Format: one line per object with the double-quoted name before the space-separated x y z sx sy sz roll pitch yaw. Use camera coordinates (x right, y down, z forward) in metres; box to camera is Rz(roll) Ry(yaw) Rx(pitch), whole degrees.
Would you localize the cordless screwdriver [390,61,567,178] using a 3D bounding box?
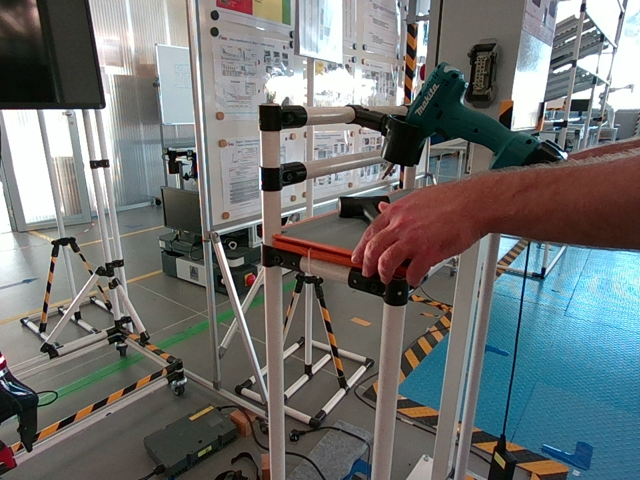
"cordless screwdriver" 0.229 -0.140 0.654 0.249 0.160 0.074 45 37 19
